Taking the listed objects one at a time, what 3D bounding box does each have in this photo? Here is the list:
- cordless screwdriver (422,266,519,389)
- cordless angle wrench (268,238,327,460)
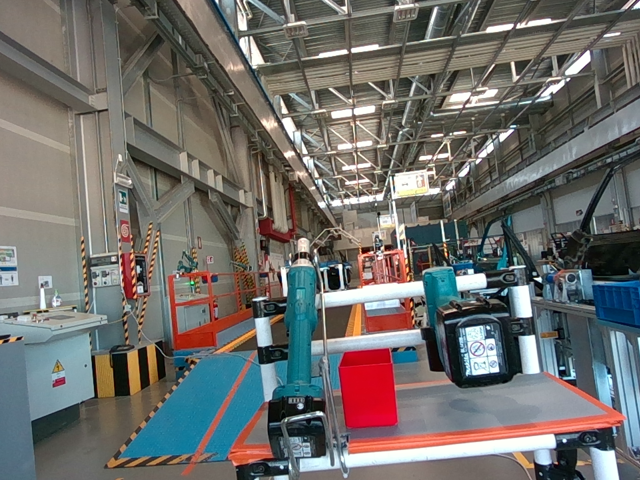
[{"bbox_3d":[0.188,0.131,0.576,0.074,0.159,0.248,-8,4,6],"label":"cordless screwdriver"},{"bbox_3d":[-0.031,0.133,0.702,0.074,0.098,0.421,-2,38,0],"label":"cordless angle wrench"}]
